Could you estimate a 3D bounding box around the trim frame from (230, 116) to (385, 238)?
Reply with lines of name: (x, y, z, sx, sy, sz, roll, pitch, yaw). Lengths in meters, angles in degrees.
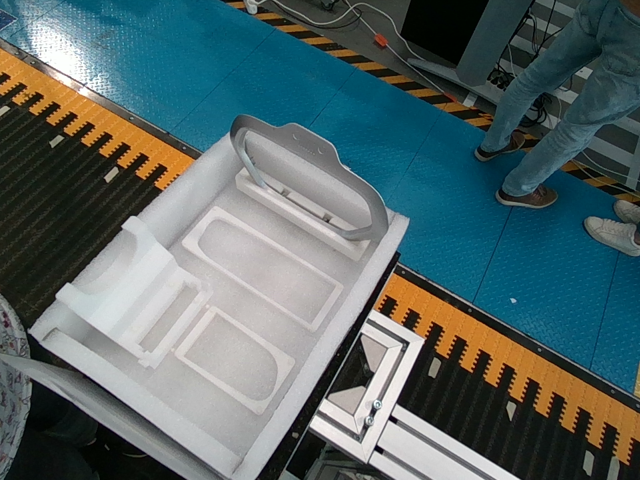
trim frame: (-0.020, -0.080, 0.576, 0.249, 0.027, 0.184, 32, -22, 11)
